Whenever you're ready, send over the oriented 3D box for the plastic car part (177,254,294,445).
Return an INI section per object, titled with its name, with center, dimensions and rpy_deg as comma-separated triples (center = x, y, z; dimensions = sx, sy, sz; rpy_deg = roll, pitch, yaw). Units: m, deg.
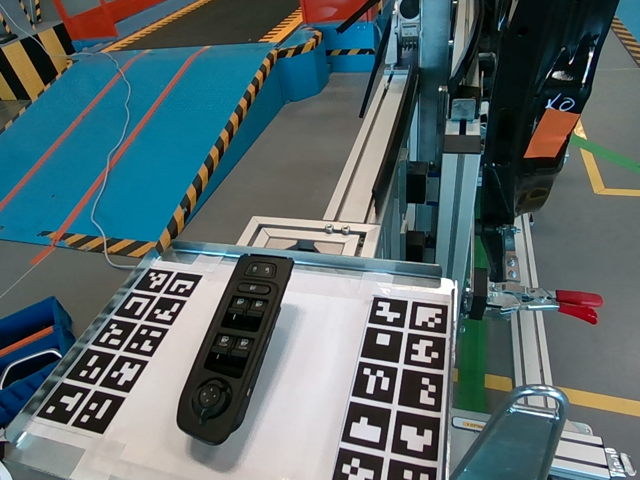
[plastic car part]
center = -0.082, 0.107, 0.440
dimensions = 0.066, 0.202, 0.067
rpy_deg = 10, -43, 10
